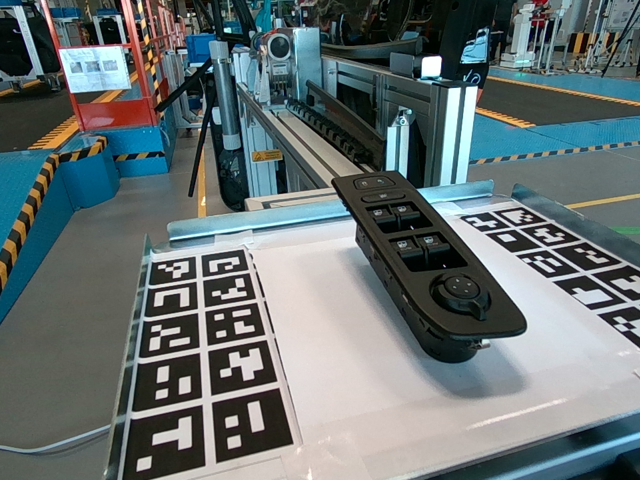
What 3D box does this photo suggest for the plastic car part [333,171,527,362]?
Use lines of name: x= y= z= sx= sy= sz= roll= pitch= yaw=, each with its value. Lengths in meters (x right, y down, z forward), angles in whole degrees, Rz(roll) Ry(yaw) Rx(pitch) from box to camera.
plastic car part: x=0.067 y=0.014 z=0.326 sx=0.066 sy=0.067 sz=0.203 roll=-3 pitch=31 yaw=-18
